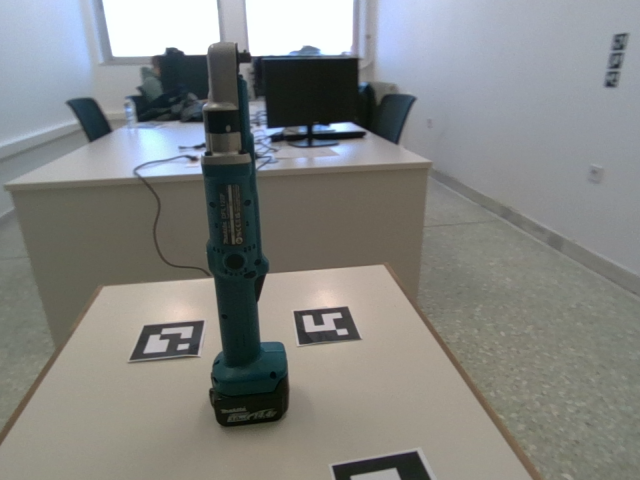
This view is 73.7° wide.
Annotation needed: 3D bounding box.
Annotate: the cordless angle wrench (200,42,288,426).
[{"bbox_3d":[-0.093,0.014,0.472,0.097,0.423,0.074,-4,22,-9],"label":"cordless angle wrench"}]
